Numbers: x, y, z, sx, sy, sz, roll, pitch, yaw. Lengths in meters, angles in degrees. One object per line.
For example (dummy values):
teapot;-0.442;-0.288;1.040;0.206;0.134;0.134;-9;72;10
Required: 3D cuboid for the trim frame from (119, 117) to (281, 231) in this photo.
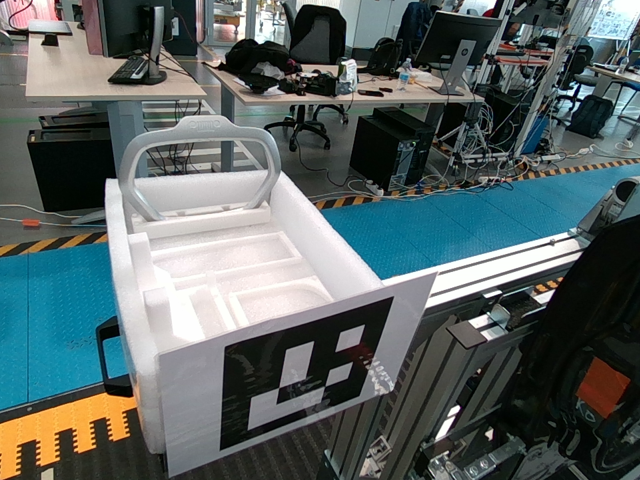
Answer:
trim frame;-0.175;-0.097;0.652;0.247;0.184;0.027;-9;40;-25
